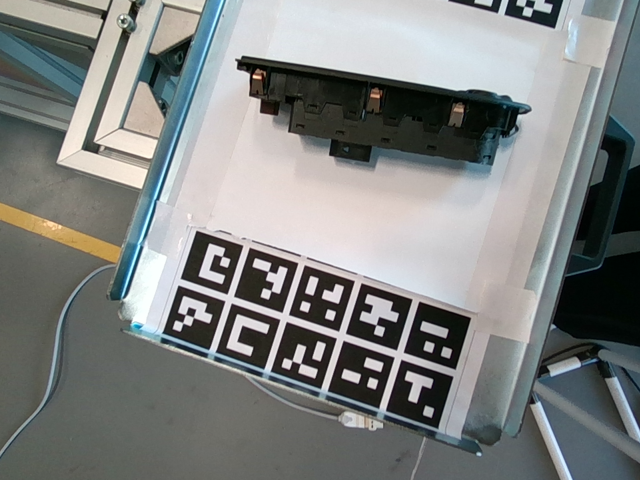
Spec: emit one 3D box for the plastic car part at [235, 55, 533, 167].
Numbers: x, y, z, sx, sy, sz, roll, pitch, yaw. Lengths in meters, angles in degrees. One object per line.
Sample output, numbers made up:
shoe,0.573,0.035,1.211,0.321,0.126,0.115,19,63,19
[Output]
plastic car part,0.044,-0.088,0.300,0.203,0.067,0.066,8,10,5
